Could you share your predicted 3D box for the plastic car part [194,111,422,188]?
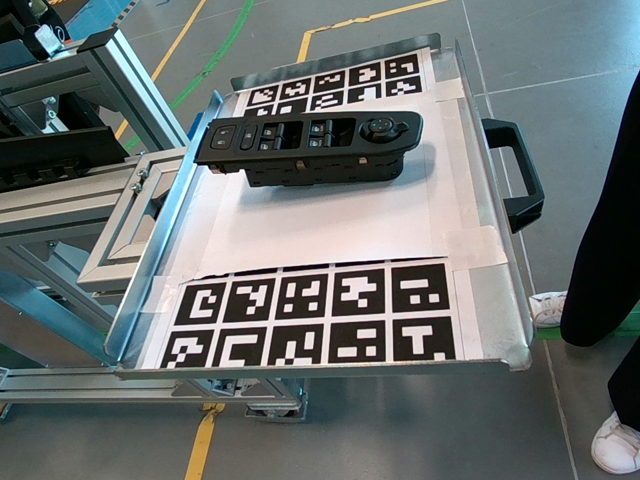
[{"bbox_3d":[-0.008,-0.080,0.399,0.204,0.067,0.066,-4,41,12],"label":"plastic car part"}]
